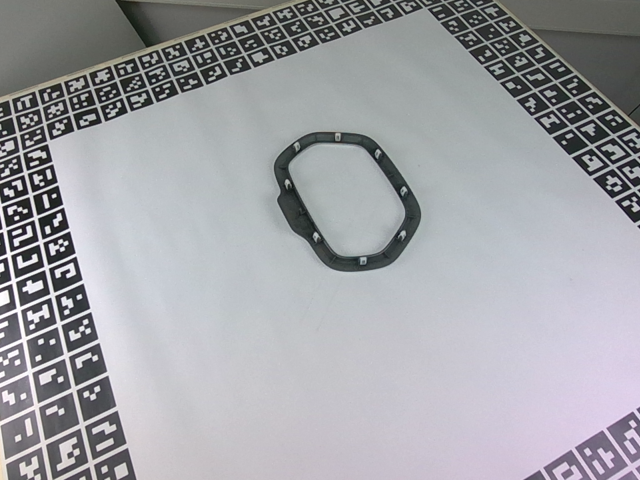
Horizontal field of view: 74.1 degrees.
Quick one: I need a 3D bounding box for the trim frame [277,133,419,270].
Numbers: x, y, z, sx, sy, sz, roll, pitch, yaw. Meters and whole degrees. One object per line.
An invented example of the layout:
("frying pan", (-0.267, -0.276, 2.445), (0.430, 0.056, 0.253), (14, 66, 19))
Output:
("trim frame", (0.035, -0.068, 0.626), (0.184, 0.248, 0.027), (-24, -23, -6))
